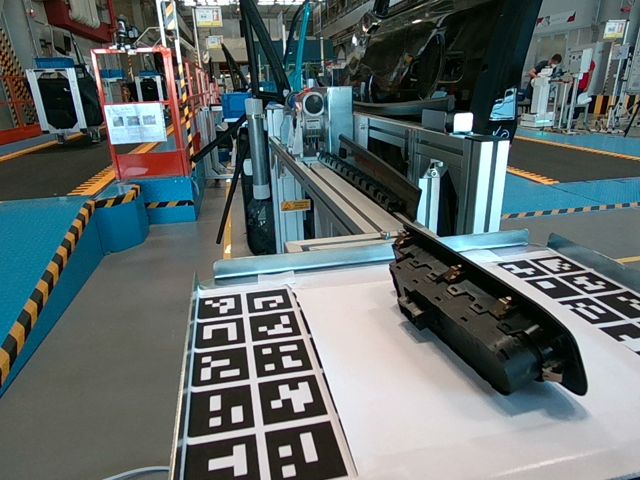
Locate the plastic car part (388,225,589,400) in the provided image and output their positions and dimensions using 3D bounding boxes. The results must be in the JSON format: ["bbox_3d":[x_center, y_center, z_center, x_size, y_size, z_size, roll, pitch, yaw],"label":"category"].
[{"bbox_3d":[0.102,0.048,0.325,0.067,0.066,0.203,-18,21,-16],"label":"plastic car part"}]
